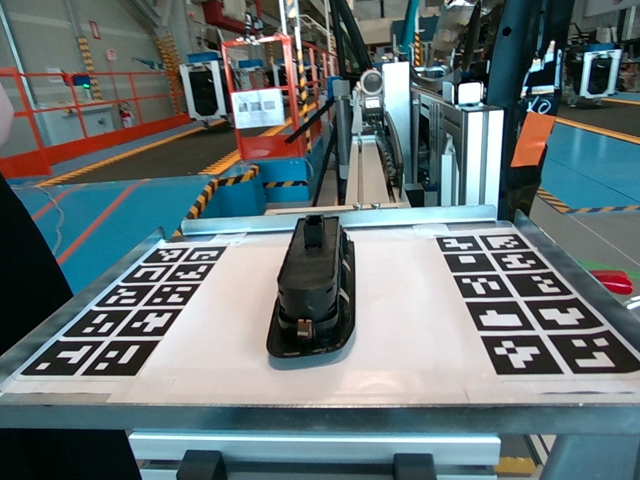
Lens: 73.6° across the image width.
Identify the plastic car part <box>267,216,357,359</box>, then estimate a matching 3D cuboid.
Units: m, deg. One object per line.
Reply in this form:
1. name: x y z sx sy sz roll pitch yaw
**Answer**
1. plastic car part: -0.002 0.022 0.357 0.066 0.067 0.202 3 25 2
